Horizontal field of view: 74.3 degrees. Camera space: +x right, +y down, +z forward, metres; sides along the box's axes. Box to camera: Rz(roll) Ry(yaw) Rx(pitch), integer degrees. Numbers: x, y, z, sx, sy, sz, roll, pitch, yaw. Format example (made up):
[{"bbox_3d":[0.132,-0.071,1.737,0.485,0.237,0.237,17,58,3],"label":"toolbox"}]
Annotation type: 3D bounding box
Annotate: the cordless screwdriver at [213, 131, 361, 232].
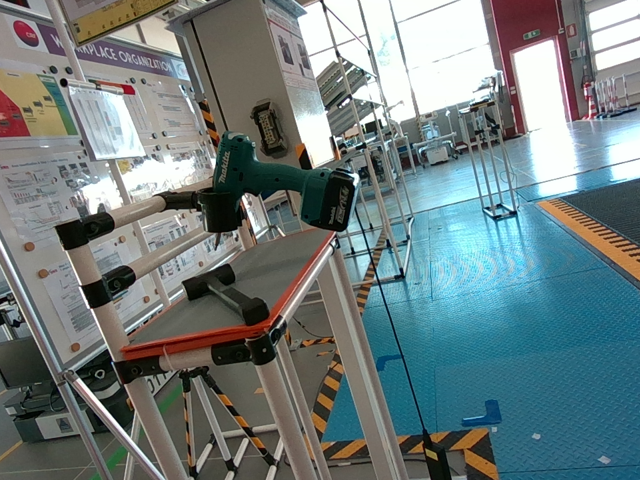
[{"bbox_3d":[-0.065,-0.074,0.717,0.249,0.159,0.074,18,22,7],"label":"cordless screwdriver"}]
